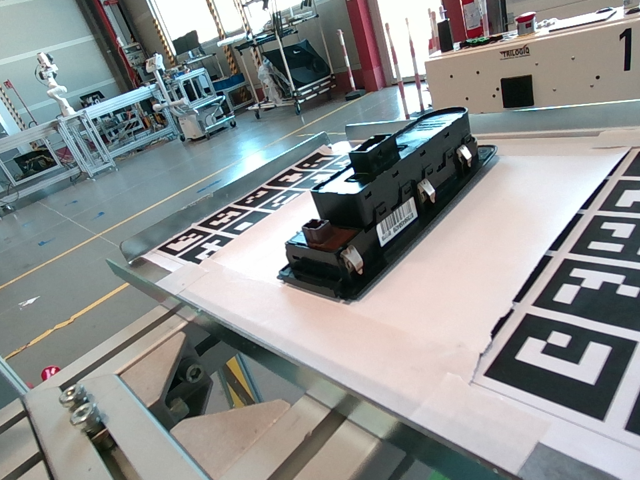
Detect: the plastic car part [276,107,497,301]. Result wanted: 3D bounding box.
[{"bbox_3d":[0.052,-0.042,0.295,0.202,0.067,0.067,-34,22,-35],"label":"plastic car part"}]
